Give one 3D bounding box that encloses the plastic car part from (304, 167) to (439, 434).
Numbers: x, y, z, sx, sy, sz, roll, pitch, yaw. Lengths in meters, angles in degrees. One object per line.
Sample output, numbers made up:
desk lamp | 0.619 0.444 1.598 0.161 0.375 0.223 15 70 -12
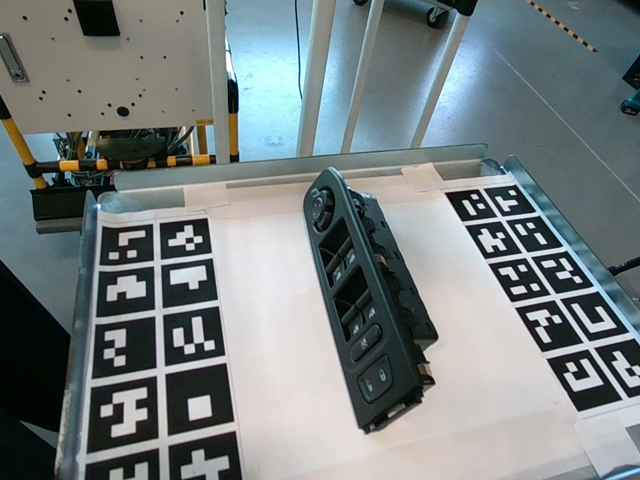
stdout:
plastic car part | 0.037 0.025 0.316 0.067 0.203 0.066 -2 -39 -25
